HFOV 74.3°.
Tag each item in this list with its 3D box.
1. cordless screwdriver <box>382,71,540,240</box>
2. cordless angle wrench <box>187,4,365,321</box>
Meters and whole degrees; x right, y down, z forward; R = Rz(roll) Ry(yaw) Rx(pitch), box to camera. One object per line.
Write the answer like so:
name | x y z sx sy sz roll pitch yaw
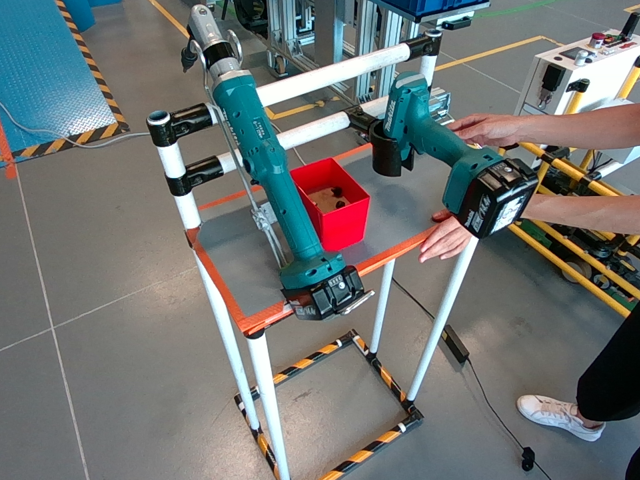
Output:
cordless screwdriver | 0.171 -0.106 0.598 0.074 0.248 0.160 -24 -31 -19
cordless angle wrench | -0.072 -0.101 0.545 0.074 0.423 0.098 -26 4 -29
